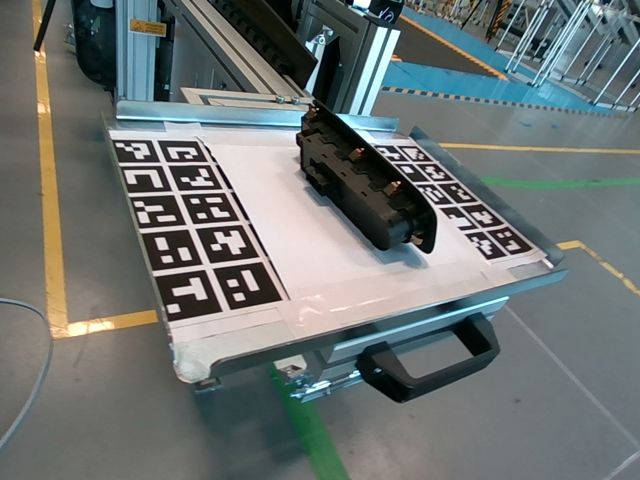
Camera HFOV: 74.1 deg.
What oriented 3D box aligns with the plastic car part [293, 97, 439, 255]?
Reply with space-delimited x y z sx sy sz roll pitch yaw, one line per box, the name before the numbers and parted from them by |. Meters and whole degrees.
plastic car part | 0.030 -0.059 0.410 0.068 0.068 0.204 -25 55 -30
